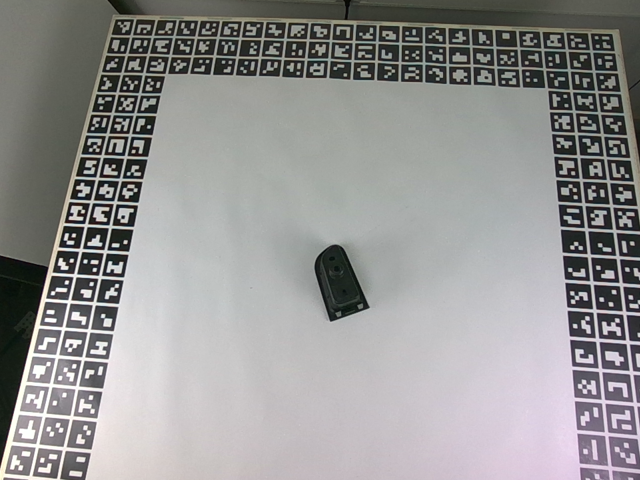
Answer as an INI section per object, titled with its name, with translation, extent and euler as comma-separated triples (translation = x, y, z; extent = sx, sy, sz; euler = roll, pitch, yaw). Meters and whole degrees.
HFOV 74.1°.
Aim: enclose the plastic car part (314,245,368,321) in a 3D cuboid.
[plastic car part]
translation = 0.027, 0.060, 0.668
extent = 0.066, 0.116, 0.071
euler = -19, -13, -4
